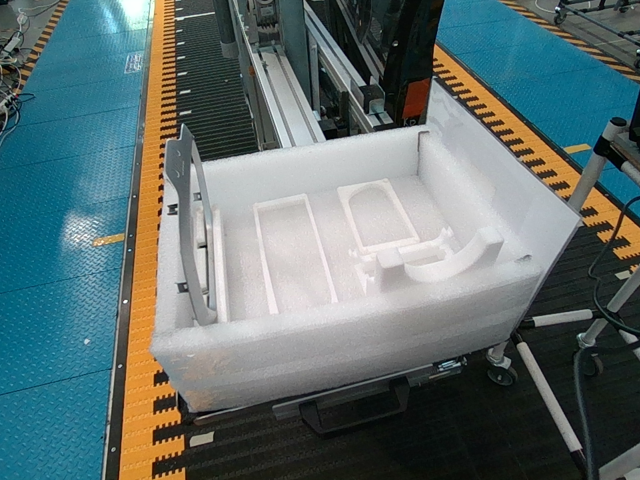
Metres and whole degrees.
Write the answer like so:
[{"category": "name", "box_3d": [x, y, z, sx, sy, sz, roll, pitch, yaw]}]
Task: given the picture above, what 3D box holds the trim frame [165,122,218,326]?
[{"category": "trim frame", "box_3d": [-0.139, -0.019, 0.470, 0.027, 0.248, 0.184, -6, -41, -7]}]
